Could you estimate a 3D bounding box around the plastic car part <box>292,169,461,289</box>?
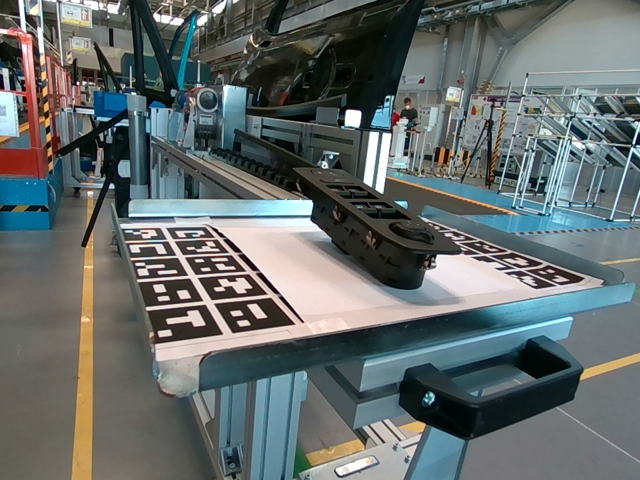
[{"bbox_3d":[0.038,-0.015,0.400,0.066,0.067,0.204,6,18,-33],"label":"plastic car part"}]
